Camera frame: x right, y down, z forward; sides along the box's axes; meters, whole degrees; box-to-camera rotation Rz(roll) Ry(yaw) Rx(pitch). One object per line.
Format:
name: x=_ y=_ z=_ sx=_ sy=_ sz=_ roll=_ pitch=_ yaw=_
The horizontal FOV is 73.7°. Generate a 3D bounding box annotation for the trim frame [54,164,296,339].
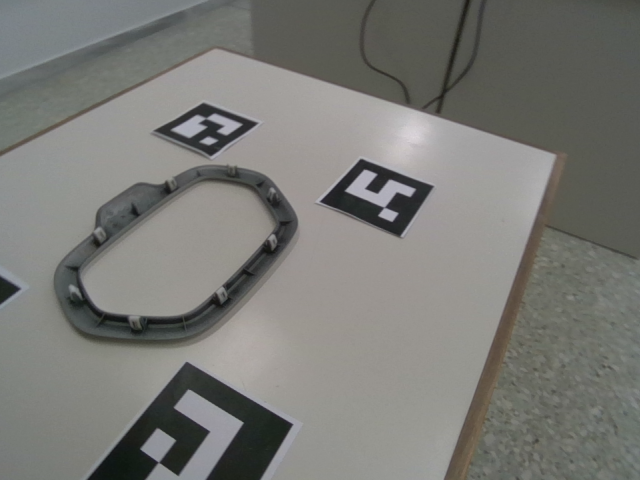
trim frame: x=-0.136 y=-0.005 z=0.425 sx=0.185 sy=0.027 sz=0.247 roll=26 pitch=52 yaw=20
